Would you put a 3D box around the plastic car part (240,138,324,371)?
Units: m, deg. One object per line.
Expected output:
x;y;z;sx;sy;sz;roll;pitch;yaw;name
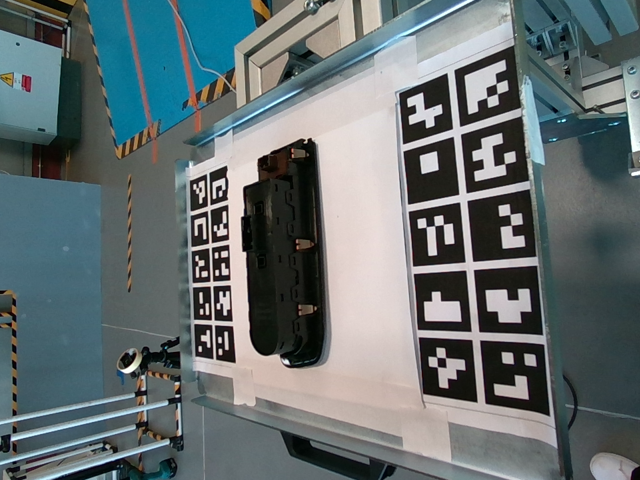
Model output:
-0.034;0.014;0.369;0.067;0.203;0.066;-10;-6;38;plastic car part
